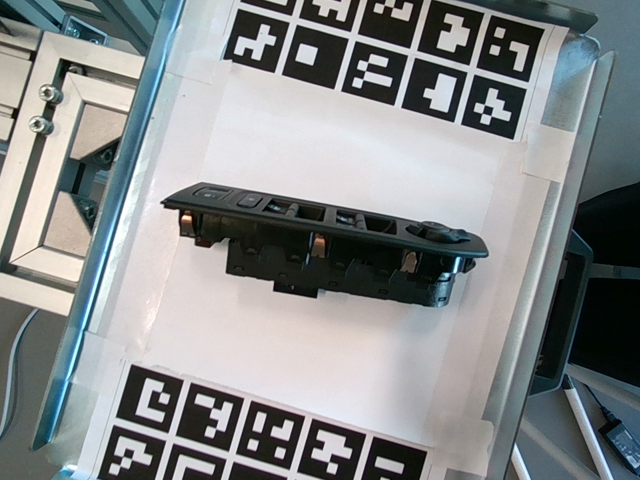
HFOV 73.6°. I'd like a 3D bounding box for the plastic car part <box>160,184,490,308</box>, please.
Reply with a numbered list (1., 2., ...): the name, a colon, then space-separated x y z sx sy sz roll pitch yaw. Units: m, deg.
1. plastic car part: 0.005 0.006 0.277 0.203 0.067 0.066 6 8 6
